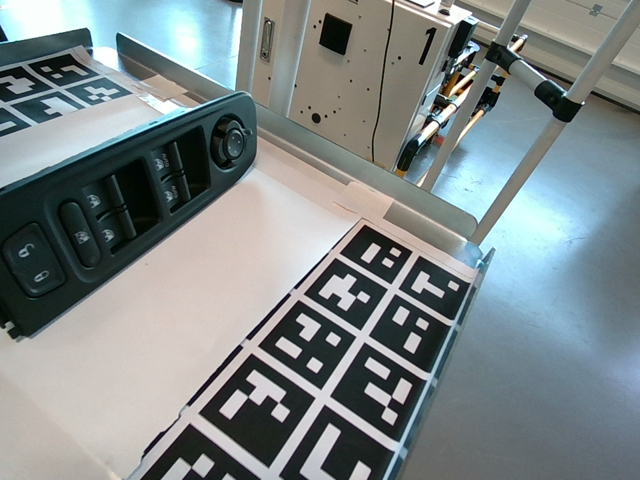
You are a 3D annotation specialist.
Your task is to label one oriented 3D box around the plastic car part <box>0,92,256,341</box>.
[{"bbox_3d":[-0.112,-0.034,0.259,0.068,0.067,0.202,11,38,34],"label":"plastic car part"}]
